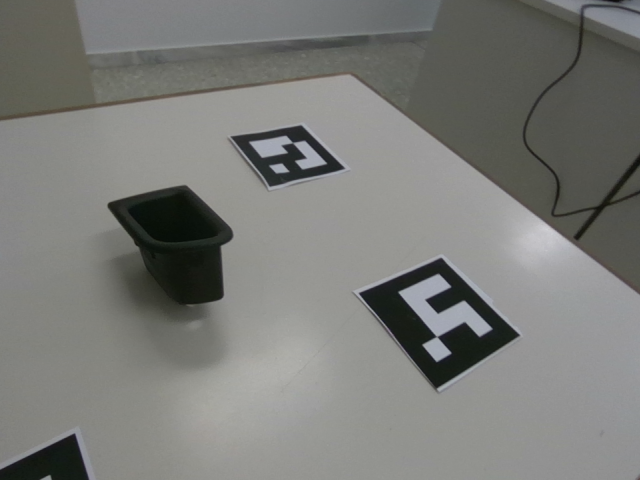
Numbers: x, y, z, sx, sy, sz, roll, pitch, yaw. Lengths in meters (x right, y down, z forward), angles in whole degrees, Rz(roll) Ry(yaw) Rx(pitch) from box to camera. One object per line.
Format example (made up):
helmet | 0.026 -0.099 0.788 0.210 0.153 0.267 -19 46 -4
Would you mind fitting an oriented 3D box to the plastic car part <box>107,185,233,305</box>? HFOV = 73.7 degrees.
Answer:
plastic car part | -0.106 0.010 0.319 0.065 0.071 0.117 -20 35 -28
